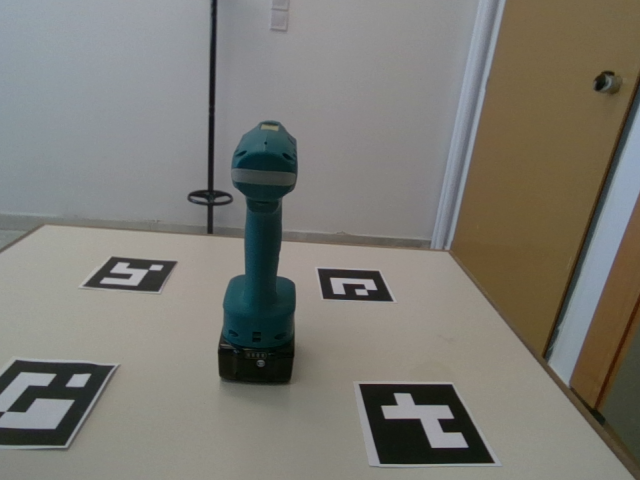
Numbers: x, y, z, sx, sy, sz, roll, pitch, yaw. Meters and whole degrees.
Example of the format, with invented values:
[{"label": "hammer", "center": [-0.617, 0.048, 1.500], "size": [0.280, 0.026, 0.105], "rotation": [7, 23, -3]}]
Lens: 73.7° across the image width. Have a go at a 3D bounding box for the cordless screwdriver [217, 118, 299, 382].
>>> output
[{"label": "cordless screwdriver", "center": [-0.055, 0.007, 0.428], "size": [0.074, 0.249, 0.159], "rotation": [5, 26, -4]}]
